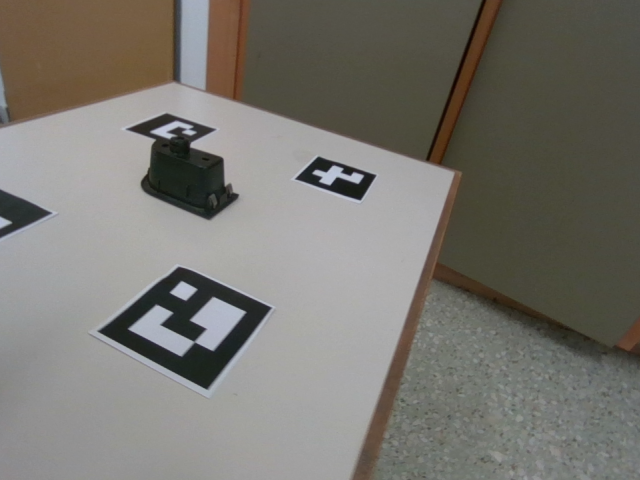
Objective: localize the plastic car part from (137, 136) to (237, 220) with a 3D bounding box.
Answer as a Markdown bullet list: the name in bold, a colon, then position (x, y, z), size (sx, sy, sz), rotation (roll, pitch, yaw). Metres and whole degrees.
- **plastic car part**: position (-0.158, -0.081, 0.494), size (0.117, 0.071, 0.065), rotation (23, 33, 9)
